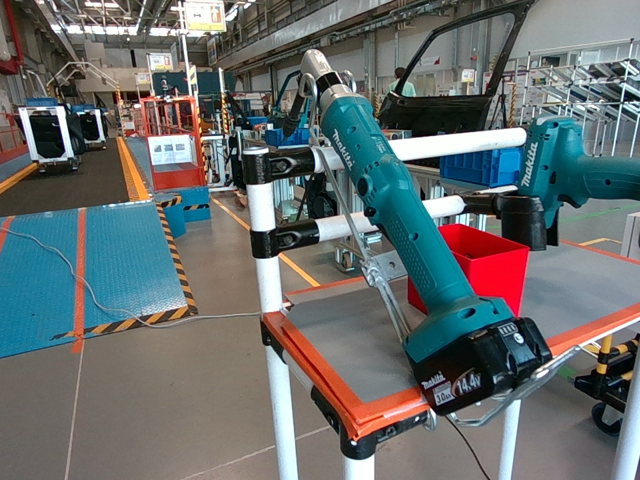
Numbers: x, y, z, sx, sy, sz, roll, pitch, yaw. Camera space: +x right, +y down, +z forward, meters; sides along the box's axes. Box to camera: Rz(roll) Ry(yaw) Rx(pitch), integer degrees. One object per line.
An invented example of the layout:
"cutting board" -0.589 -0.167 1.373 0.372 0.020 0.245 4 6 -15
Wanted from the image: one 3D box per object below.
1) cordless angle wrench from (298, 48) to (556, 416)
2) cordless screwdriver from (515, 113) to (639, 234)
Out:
"cordless angle wrench" 0.063 -0.052 0.427 0.074 0.422 0.098 -9 -29 -29
"cordless screwdriver" 0.314 -0.033 0.445 0.074 0.159 0.248 -12 29 -23
